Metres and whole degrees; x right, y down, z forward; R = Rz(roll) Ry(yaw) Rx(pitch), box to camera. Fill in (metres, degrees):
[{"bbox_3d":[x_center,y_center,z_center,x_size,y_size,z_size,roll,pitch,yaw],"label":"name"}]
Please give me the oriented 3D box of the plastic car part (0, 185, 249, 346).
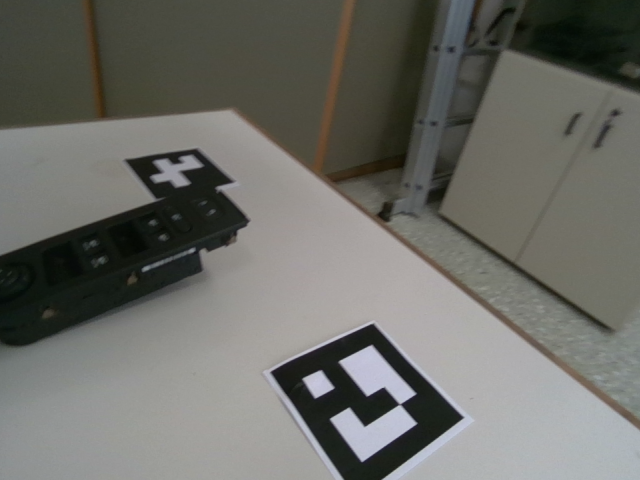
[{"bbox_3d":[-0.158,0.019,0.322,0.201,0.067,0.067,-21,56,-32],"label":"plastic car part"}]
